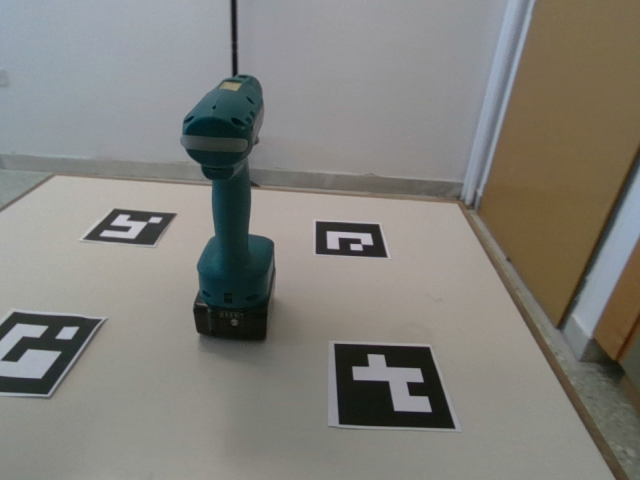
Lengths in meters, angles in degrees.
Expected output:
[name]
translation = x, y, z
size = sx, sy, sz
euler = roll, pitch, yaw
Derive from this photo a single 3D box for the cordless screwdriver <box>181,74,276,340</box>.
[cordless screwdriver]
translation = -0.080, -0.030, 0.426
size = 0.074, 0.249, 0.159
euler = 5, 34, 0
